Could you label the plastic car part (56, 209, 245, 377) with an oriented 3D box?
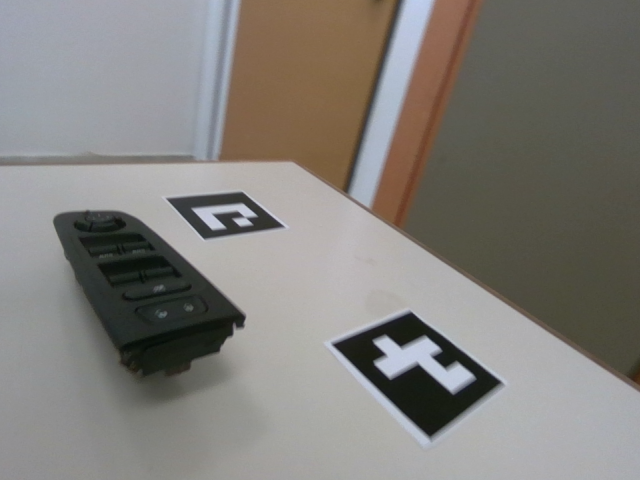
[{"bbox_3d":[-0.127,0.029,0.291,0.066,0.067,0.205,-18,37,-34],"label":"plastic car part"}]
